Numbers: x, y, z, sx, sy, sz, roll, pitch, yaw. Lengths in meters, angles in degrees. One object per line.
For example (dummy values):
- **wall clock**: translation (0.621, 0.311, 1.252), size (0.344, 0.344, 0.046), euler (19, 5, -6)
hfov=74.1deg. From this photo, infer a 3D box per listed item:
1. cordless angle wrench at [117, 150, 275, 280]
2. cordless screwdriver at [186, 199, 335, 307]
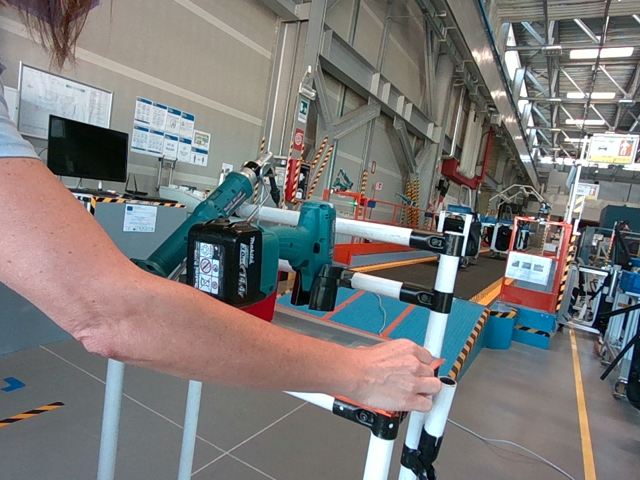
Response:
- **cordless angle wrench**: translation (-0.201, -0.039, 0.763), size (0.074, 0.098, 0.421), euler (15, 50, 26)
- **cordless screwdriver**: translation (-0.058, 0.034, 0.568), size (0.074, 0.159, 0.248), euler (8, 14, 32)
